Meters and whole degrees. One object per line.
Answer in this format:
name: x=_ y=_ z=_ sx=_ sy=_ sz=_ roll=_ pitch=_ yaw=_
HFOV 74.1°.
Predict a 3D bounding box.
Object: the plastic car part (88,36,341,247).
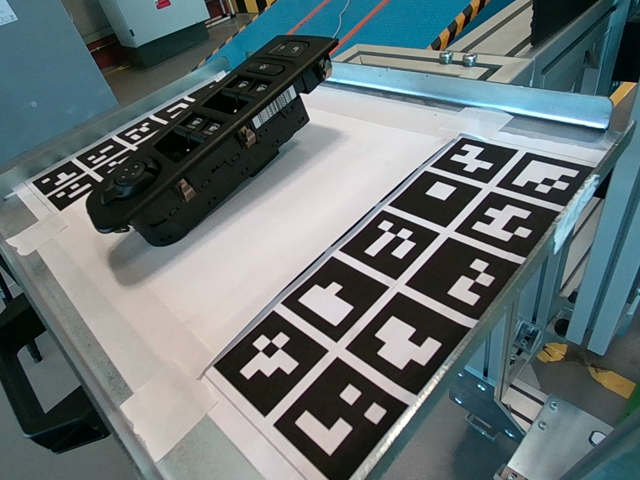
plastic car part: x=-0.067 y=-0.068 z=0.298 sx=0.066 sy=0.202 sz=0.067 roll=31 pitch=-27 yaw=31
